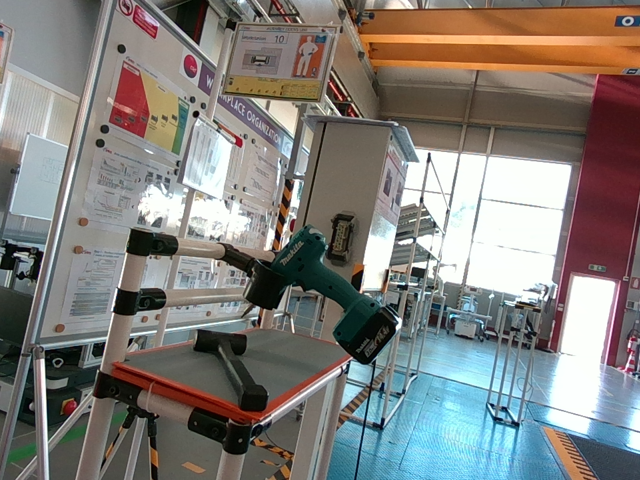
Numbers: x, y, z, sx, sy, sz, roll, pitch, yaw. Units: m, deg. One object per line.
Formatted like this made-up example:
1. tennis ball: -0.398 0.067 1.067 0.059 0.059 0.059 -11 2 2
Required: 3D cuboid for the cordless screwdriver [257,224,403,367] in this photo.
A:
1. cordless screwdriver: 0.010 0.109 0.725 0.248 0.159 0.074 45 11 17
